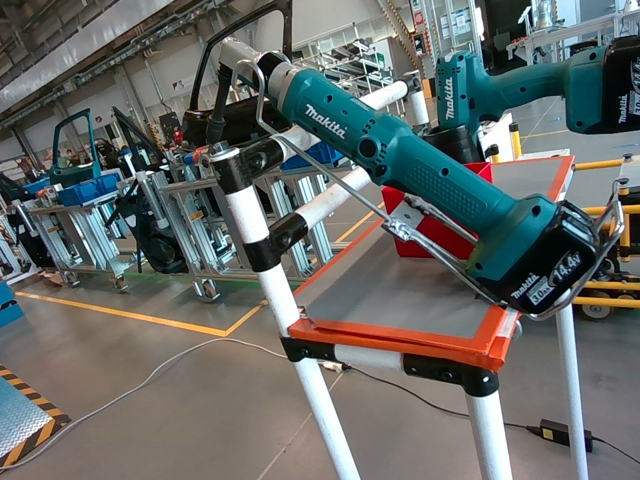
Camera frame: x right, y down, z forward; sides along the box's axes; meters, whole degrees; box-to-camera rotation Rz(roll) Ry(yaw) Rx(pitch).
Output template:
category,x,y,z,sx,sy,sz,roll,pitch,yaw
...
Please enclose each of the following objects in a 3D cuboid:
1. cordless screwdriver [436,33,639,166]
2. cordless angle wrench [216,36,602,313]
category,x,y,z,sx,sy,sz,roll,pitch,yaw
cordless screwdriver,0.271,-0.166,0.538,0.249,0.159,0.074,10,32,36
cordless angle wrench,0.058,-0.094,0.423,0.423,0.098,0.074,36,38,12
